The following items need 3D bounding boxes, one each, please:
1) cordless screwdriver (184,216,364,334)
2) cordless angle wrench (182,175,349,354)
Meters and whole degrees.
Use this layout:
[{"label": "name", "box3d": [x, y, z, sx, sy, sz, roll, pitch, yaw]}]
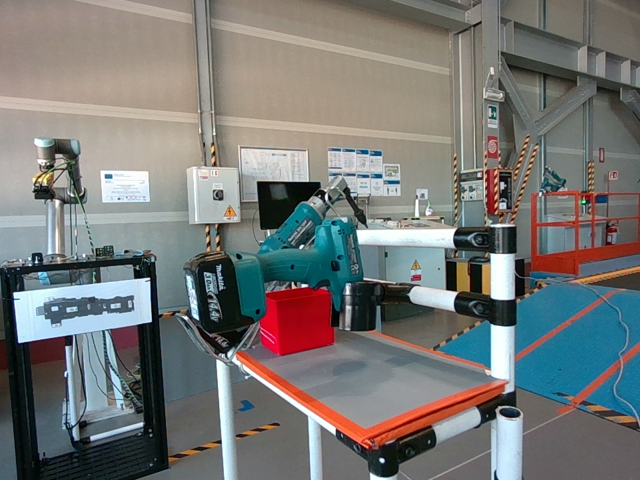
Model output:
[{"label": "cordless screwdriver", "box3d": [-0.046, 0.066, 0.569, 0.248, 0.159, 0.074, -14, 7, -29]}, {"label": "cordless angle wrench", "box3d": [-0.080, 0.021, 0.814, 0.074, 0.422, 0.098, 13, -33, 53]}]
